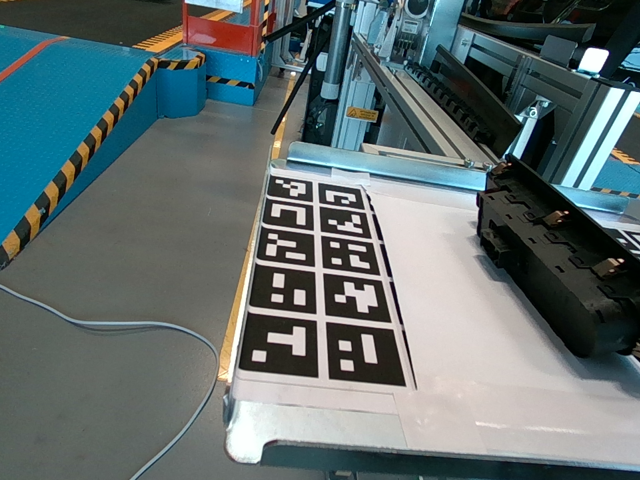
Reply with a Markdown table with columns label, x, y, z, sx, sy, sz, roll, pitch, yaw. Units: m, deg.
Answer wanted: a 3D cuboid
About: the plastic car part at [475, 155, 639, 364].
| label | x | y | z | sx | sy | sz | roll | pitch | yaw |
| --- | --- | --- | --- | --- | --- | --- | --- | --- | --- |
| plastic car part | 0.159 | 0.008 | 0.302 | 0.067 | 0.066 | 0.203 | -6 | 34 | -10 |
